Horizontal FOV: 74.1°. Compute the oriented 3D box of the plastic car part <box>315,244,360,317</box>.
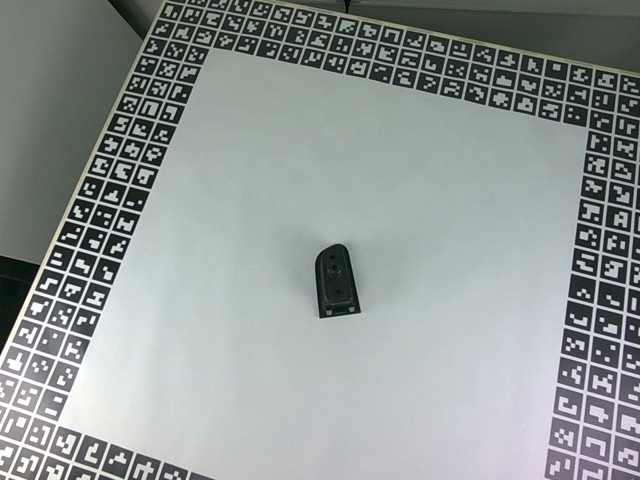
[{"bbox_3d":[0.024,0.058,0.664,0.066,0.116,0.071,-7,-12,0],"label":"plastic car part"}]
